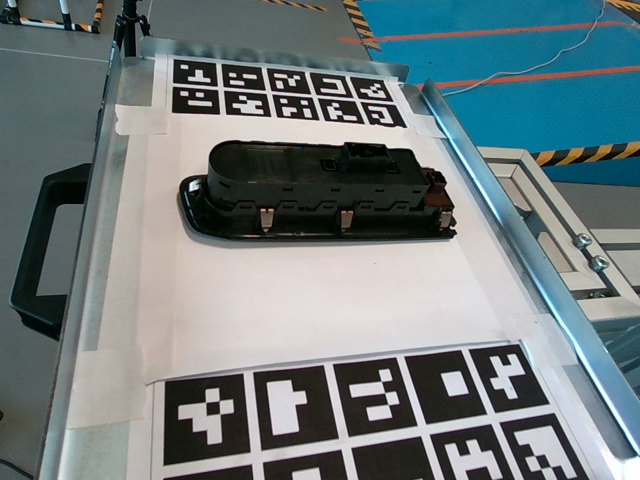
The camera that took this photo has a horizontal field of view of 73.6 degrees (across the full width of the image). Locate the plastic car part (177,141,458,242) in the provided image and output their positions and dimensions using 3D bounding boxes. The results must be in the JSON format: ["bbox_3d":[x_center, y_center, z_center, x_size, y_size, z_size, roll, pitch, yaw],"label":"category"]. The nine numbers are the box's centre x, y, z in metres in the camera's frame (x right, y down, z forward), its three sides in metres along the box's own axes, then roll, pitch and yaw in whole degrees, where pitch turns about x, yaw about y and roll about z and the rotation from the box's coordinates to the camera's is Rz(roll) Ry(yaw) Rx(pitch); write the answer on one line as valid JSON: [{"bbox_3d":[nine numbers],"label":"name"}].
[{"bbox_3d":[0.006,-0.035,0.296,0.202,0.066,0.067,-4,-32,-15],"label":"plastic car part"}]
